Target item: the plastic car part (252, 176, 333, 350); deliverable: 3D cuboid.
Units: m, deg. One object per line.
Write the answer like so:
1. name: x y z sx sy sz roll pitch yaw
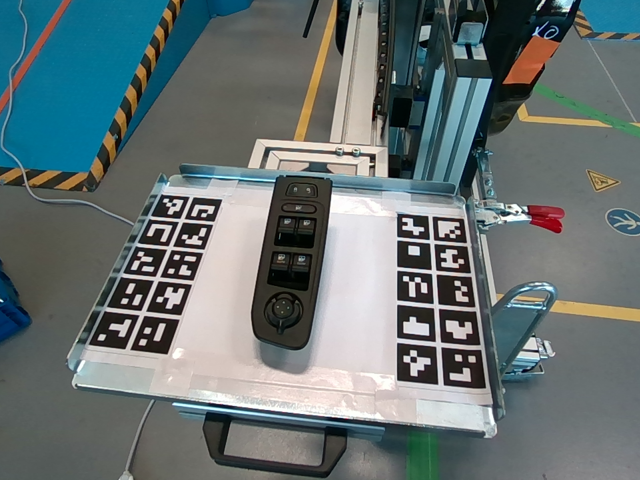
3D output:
1. plastic car part: -0.030 0.024 0.462 0.066 0.202 0.067 8 -35 -2
